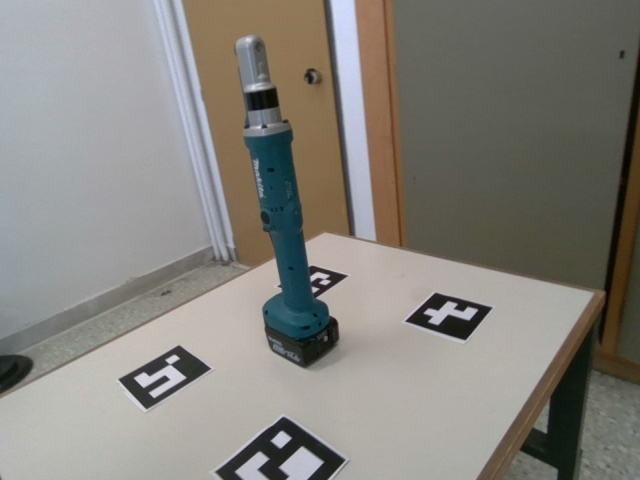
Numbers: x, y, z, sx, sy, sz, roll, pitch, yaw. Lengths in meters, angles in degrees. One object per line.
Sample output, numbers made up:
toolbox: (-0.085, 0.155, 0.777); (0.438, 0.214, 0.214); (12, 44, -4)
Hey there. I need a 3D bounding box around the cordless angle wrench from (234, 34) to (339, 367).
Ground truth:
cordless angle wrench: (-0.052, -0.036, 0.557); (0.099, 0.422, 0.073); (13, 29, 43)
